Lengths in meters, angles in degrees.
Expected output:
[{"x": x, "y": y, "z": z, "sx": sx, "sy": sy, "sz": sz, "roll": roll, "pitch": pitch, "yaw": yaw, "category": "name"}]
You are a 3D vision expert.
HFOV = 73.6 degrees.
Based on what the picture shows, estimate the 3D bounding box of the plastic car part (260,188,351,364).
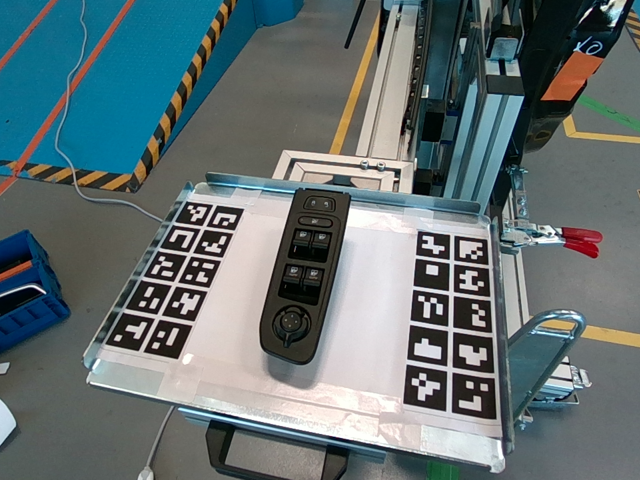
[{"x": -0.016, "y": 0.038, "z": 0.462, "sx": 0.066, "sy": 0.202, "sz": 0.067, "roll": 11, "pitch": -35, "yaw": 3, "category": "plastic car part"}]
